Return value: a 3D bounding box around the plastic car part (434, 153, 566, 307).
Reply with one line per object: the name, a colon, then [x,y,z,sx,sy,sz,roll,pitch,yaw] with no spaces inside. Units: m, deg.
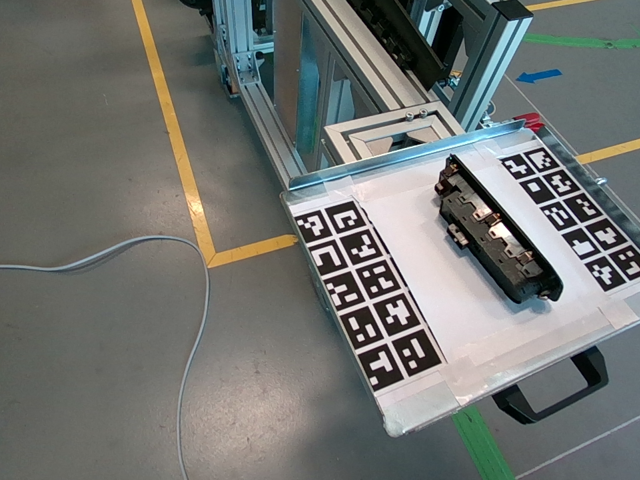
plastic car part: [0.194,-0.005,0.493,0.067,0.203,0.066,-33,-22,-10]
